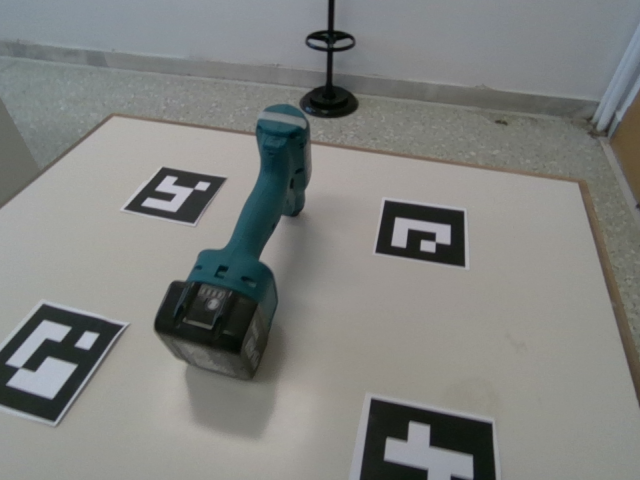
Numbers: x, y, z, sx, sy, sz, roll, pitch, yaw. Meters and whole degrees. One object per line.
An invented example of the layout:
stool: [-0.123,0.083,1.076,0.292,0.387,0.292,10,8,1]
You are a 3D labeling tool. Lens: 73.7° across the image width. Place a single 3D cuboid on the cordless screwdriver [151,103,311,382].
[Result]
cordless screwdriver: [-0.062,0.007,0.419,0.074,0.248,0.159,13,-29,8]
